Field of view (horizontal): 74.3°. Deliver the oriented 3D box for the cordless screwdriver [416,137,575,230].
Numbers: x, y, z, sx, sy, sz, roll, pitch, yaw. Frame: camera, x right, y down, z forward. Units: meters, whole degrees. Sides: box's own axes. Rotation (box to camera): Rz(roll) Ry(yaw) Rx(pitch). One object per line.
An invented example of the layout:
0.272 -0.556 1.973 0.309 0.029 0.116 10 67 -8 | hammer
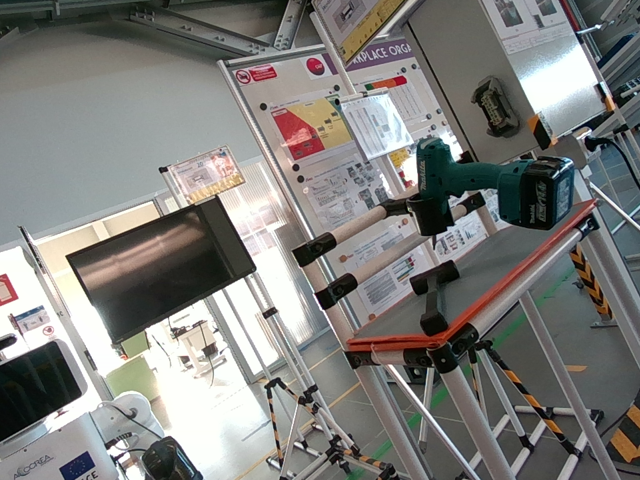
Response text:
0.265 -0.074 0.689 0.074 0.159 0.249 -30 35 -33 | cordless screwdriver
